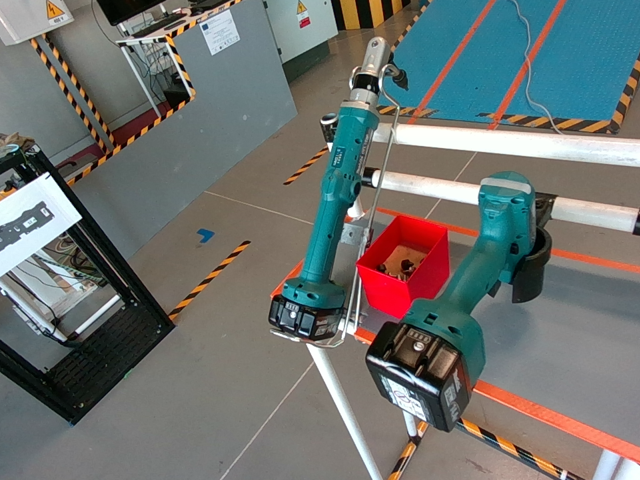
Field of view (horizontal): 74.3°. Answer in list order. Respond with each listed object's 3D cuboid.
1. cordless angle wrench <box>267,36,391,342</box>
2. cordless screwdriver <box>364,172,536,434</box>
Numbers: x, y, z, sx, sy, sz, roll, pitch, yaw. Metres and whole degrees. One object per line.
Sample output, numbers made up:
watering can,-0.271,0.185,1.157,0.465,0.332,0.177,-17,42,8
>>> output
cordless angle wrench,0.029,-0.074,0.589,0.074,0.423,0.098,16,3,27
cordless screwdriver,0.153,0.068,0.430,0.074,0.248,0.159,18,-31,40
